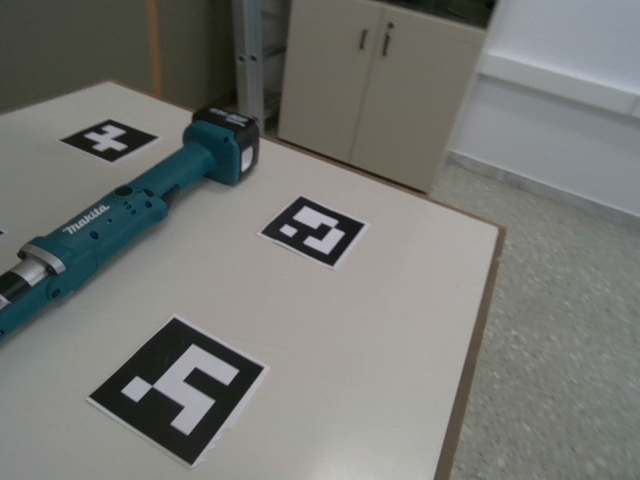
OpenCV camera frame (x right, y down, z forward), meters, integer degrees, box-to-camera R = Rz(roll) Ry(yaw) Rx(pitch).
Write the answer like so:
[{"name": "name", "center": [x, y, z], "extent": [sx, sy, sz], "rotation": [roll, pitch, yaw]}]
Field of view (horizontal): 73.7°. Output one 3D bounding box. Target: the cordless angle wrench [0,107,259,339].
[{"name": "cordless angle wrench", "center": [-0.211, -0.032, 0.475], "extent": [0.098, 0.074, 0.420], "rotation": [22, 43, 13]}]
